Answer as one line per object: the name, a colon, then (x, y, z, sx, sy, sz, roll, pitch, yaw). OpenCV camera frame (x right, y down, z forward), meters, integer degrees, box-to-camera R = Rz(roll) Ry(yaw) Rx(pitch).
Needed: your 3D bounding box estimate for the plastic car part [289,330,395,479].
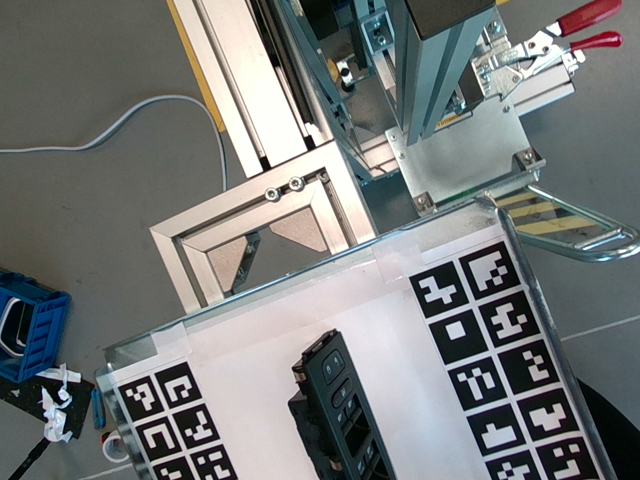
plastic car part: (0.020, 0.191, 0.379, 0.067, 0.203, 0.066, -26, -2, 22)
